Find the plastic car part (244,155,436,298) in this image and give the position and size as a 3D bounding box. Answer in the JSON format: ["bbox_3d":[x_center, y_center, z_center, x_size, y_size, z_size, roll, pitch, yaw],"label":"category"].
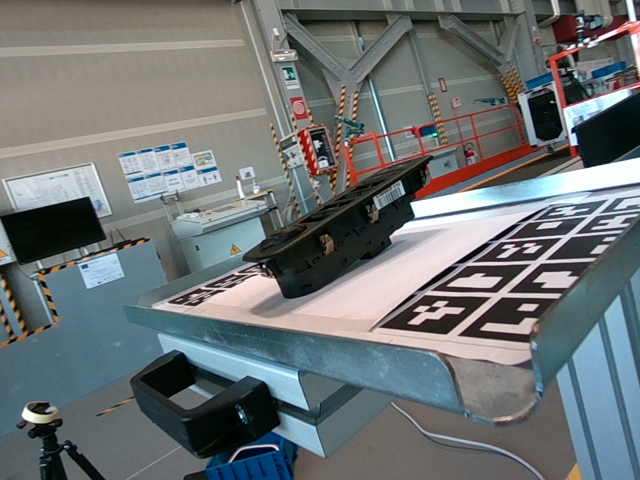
[{"bbox_3d":[0.024,-0.012,0.366,0.201,0.067,0.067,-28,20,-36],"label":"plastic car part"}]
